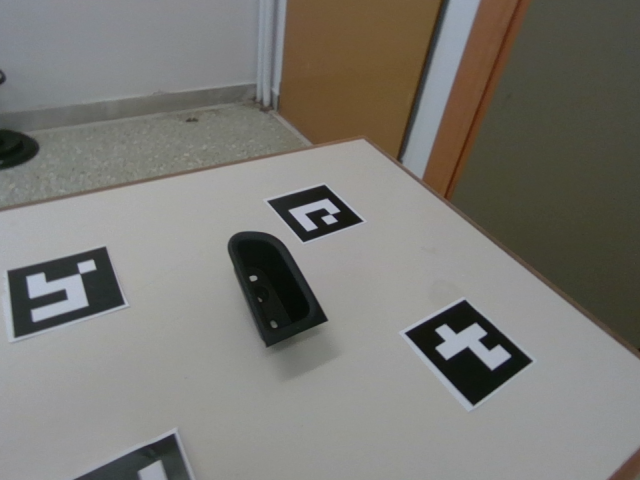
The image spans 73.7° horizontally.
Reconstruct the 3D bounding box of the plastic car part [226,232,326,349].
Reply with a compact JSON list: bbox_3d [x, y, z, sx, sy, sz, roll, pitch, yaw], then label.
[{"bbox_3d":[-0.055,0.054,0.435,0.065,0.117,0.071,-18,-26,-26],"label":"plastic car part"}]
